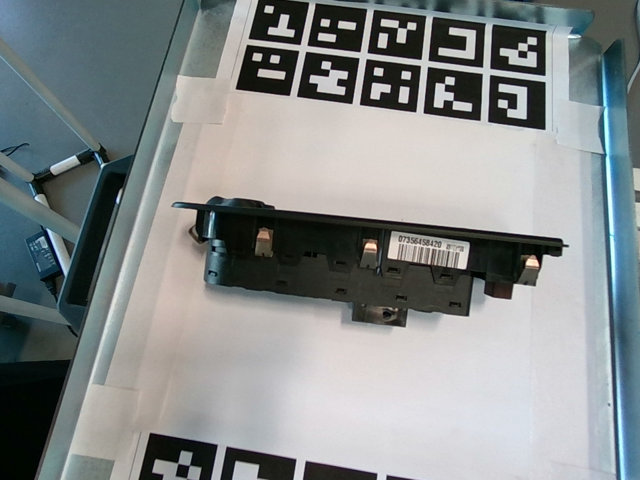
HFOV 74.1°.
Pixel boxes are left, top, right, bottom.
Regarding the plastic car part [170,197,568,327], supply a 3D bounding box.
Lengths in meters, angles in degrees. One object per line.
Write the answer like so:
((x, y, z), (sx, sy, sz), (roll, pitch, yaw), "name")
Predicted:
((0.018, 0.011, 0.243), (0.203, 0.067, 0.066), (10, 8, 2), "plastic car part")
